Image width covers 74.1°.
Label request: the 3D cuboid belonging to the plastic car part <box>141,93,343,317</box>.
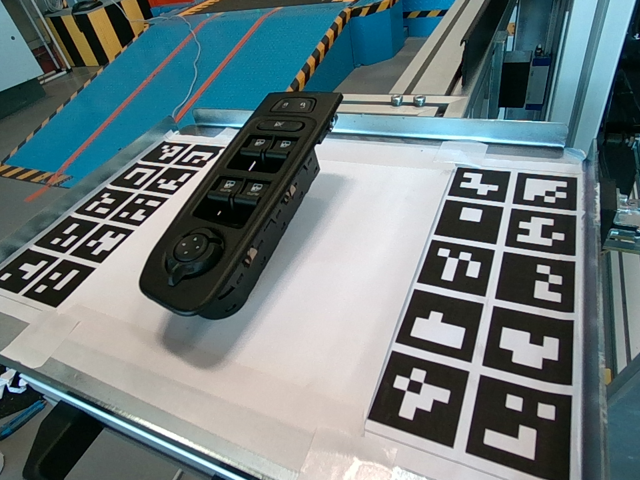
[{"bbox_3d":[-0.047,-0.028,0.297,0.066,0.202,0.067,15,-39,18],"label":"plastic car part"}]
